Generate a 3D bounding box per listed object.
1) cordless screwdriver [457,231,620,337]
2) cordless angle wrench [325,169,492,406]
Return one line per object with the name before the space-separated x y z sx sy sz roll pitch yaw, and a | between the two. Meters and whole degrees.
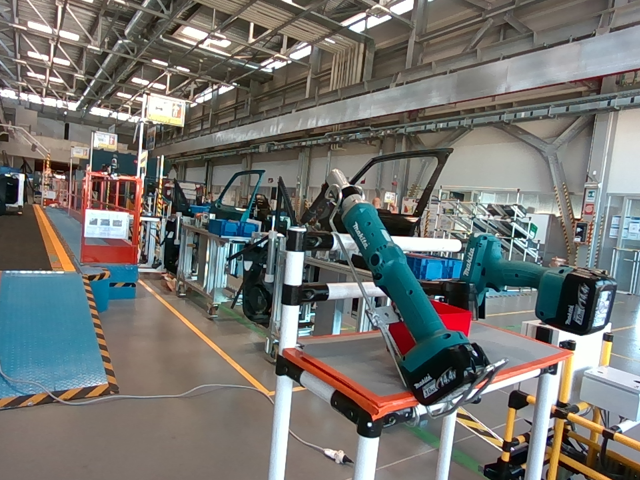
cordless screwdriver | 0.336 0.090 0.702 0.074 0.159 0.249 2 14 -33
cordless angle wrench | 0.102 0.036 0.659 0.074 0.422 0.098 7 -45 -41
